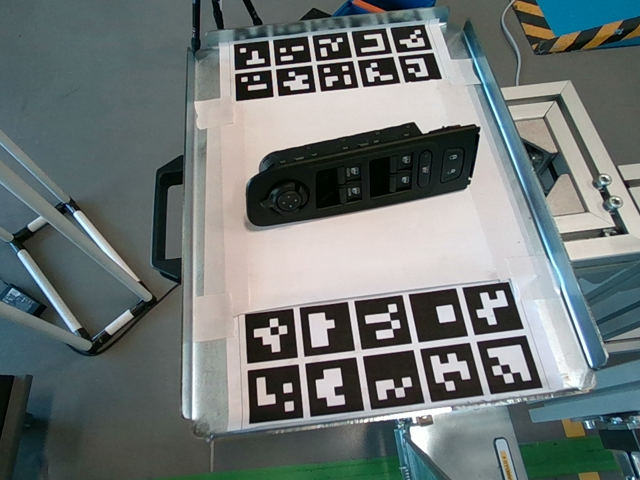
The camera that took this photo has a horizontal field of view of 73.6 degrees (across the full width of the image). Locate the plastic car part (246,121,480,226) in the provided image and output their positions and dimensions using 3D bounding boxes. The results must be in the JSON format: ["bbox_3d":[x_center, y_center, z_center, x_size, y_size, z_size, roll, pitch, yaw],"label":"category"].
[{"bbox_3d":[0.030,-0.065,0.376,0.203,0.067,0.066,-15,-37,-6],"label":"plastic car part"}]
